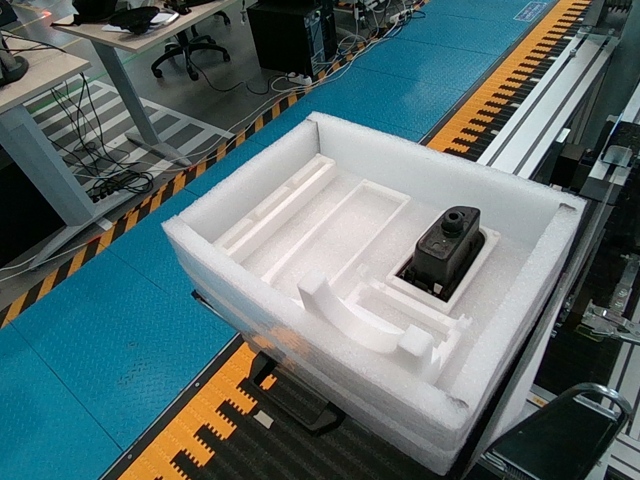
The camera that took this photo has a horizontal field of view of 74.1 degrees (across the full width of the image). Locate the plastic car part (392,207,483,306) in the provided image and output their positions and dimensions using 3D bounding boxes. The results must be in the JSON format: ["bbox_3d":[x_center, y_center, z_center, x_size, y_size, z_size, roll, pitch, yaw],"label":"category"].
[{"bbox_3d":[0.141,0.003,0.477,0.066,0.116,0.071,29,-29,30],"label":"plastic car part"}]
